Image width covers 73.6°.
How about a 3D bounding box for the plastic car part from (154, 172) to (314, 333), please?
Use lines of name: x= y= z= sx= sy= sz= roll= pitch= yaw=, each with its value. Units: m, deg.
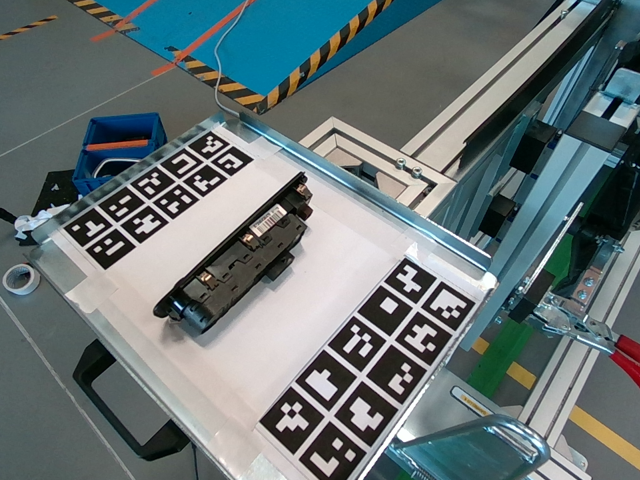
plastic car part: x=-0.072 y=0.019 z=0.427 sx=0.202 sy=0.067 sz=0.067 roll=-41 pitch=1 yaw=-27
